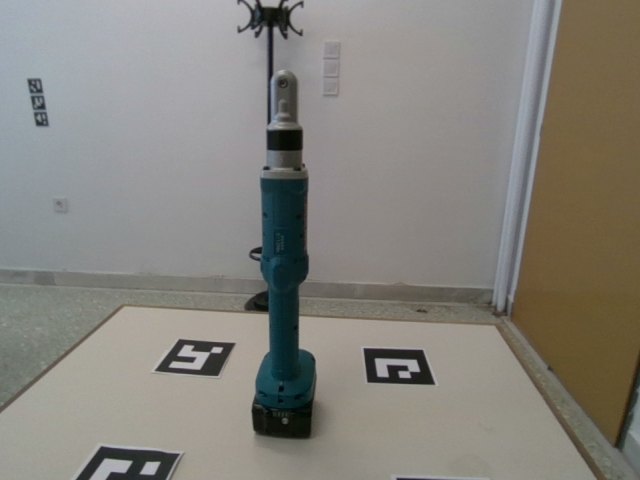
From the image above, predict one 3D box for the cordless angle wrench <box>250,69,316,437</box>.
[{"bbox_3d":[-0.041,0.028,0.498,0.074,0.423,0.098,2,16,4],"label":"cordless angle wrench"}]
